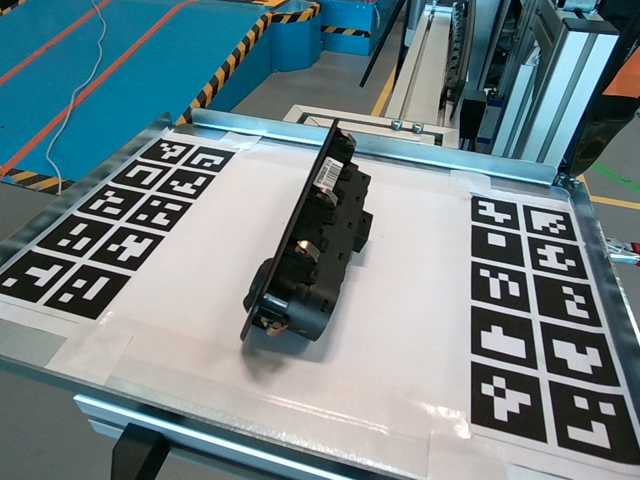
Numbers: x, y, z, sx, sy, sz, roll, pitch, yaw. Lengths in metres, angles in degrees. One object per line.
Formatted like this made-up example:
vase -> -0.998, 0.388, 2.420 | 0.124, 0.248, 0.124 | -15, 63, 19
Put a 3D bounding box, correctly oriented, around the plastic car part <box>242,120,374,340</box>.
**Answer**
plastic car part -> 0.000, -0.005, 0.304 | 0.067, 0.202, 0.067 | 33, -48, -7
